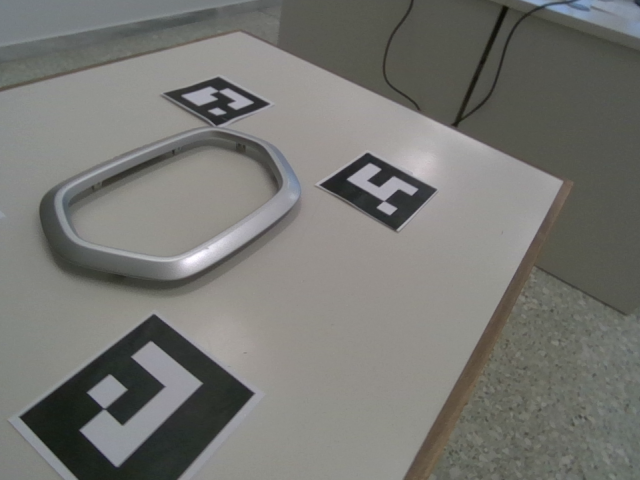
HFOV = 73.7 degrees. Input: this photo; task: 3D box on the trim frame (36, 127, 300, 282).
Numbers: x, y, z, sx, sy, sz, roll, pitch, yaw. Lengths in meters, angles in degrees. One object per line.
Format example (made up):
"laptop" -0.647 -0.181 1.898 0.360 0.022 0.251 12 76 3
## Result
"trim frame" -0.130 -0.047 0.405 0.185 0.027 0.246 32 48 18
